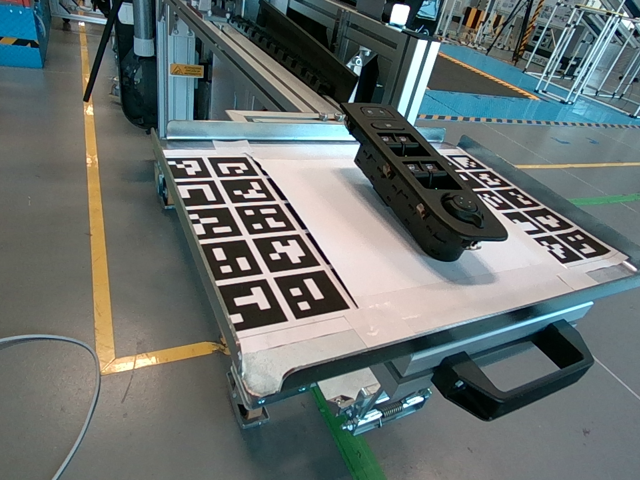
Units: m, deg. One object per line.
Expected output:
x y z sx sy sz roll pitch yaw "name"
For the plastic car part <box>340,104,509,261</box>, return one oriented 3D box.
0.081 -0.055 0.393 0.066 0.067 0.203 -1 40 -34 "plastic car part"
